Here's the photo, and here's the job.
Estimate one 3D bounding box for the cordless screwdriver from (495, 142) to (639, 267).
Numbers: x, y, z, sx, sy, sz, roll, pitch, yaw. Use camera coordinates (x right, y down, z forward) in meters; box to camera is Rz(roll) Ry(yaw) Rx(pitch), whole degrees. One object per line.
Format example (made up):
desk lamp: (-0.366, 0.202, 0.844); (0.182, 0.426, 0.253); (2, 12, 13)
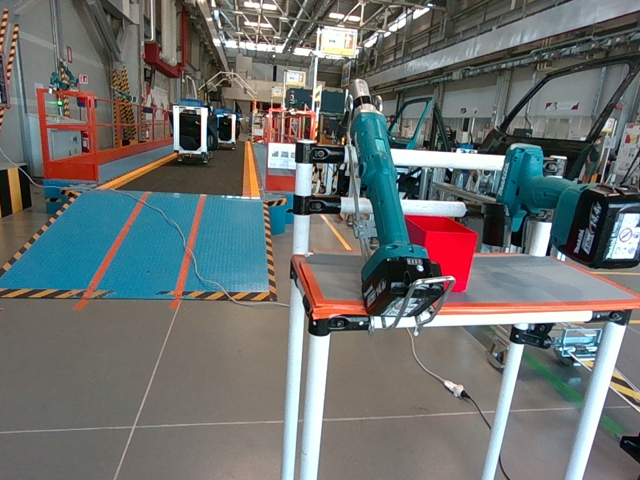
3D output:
cordless screwdriver: (0.328, -0.034, 0.596); (0.074, 0.159, 0.248); (0, 25, -9)

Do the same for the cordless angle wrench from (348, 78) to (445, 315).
cordless angle wrench: (0.085, -0.099, 0.633); (0.074, 0.422, 0.098); (3, -33, -16)
